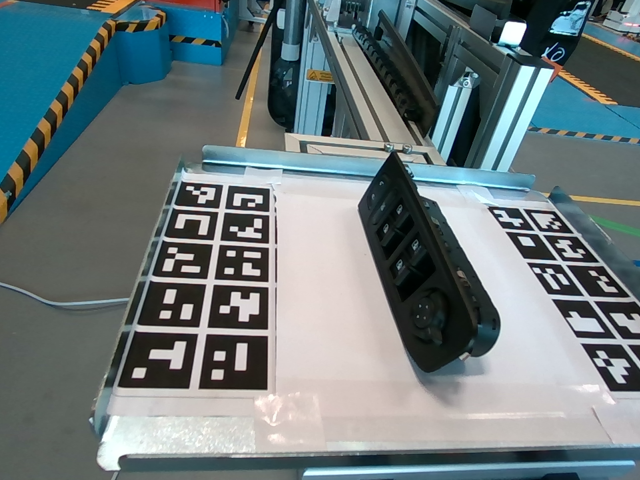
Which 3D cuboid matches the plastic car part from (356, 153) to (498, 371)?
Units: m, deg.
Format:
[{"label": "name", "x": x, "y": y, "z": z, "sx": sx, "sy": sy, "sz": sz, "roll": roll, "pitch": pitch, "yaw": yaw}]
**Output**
[{"label": "plastic car part", "x": 0.080, "y": 0.015, "z": 0.334, "sx": 0.067, "sy": 0.067, "sz": 0.203, "roll": 27, "pitch": 32, "yaw": -23}]
